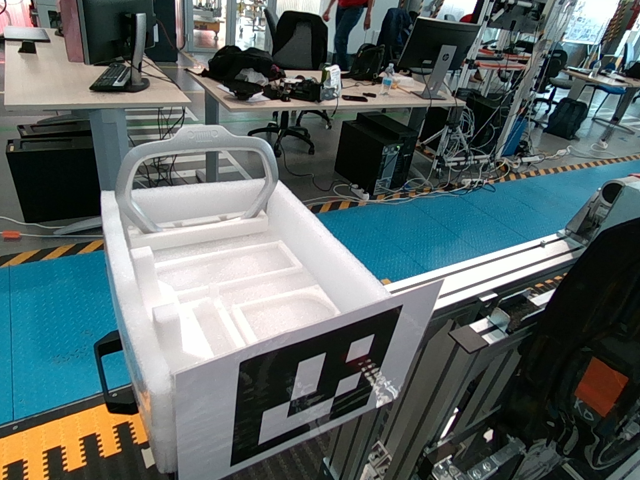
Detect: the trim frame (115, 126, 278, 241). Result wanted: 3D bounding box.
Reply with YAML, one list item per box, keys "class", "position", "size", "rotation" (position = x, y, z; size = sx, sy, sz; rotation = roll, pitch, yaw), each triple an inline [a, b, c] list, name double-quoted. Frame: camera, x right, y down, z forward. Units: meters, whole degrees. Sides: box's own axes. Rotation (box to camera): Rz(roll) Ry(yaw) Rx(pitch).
- class: "trim frame"
  position: [-0.178, -0.082, 0.646]
  size: [0.247, 0.184, 0.027]
  rotation: [-10, 41, -26]
